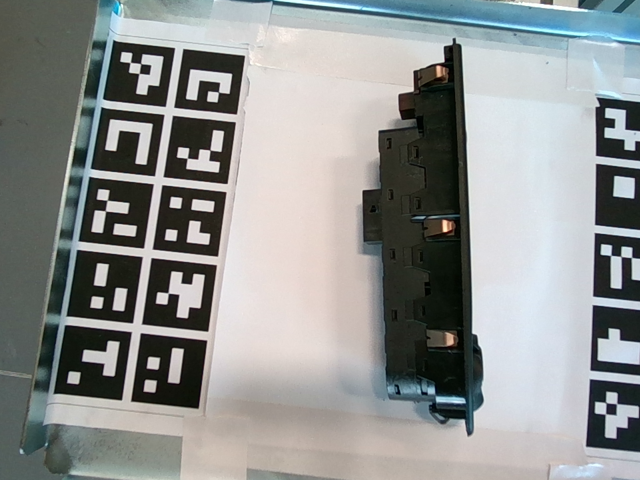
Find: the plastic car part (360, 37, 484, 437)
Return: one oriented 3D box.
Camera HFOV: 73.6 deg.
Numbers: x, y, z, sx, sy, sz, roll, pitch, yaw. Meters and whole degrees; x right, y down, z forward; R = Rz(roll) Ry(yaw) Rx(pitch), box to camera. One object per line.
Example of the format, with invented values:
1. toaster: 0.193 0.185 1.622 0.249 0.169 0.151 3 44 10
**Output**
1. plastic car part: 0.057 0.003 0.234 0.067 0.202 0.066 -5 -7 6
